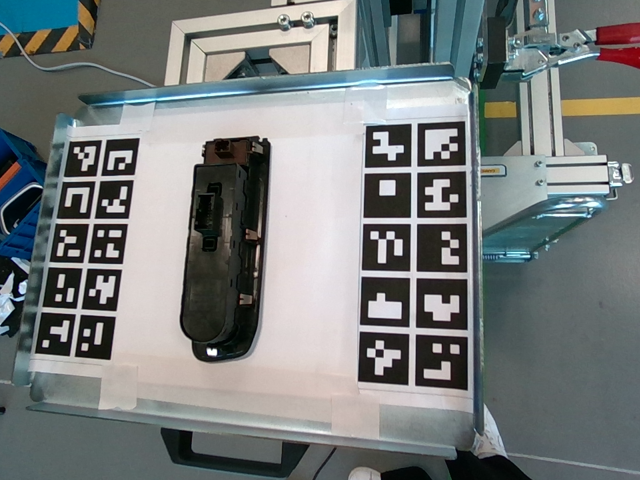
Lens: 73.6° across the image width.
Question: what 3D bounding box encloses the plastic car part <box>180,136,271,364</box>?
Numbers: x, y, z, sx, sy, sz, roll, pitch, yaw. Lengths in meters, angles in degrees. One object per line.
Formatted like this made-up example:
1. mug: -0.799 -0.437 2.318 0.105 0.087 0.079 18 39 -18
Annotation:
1. plastic car part: -0.081 0.003 0.361 0.066 0.202 0.067 0 -8 7
